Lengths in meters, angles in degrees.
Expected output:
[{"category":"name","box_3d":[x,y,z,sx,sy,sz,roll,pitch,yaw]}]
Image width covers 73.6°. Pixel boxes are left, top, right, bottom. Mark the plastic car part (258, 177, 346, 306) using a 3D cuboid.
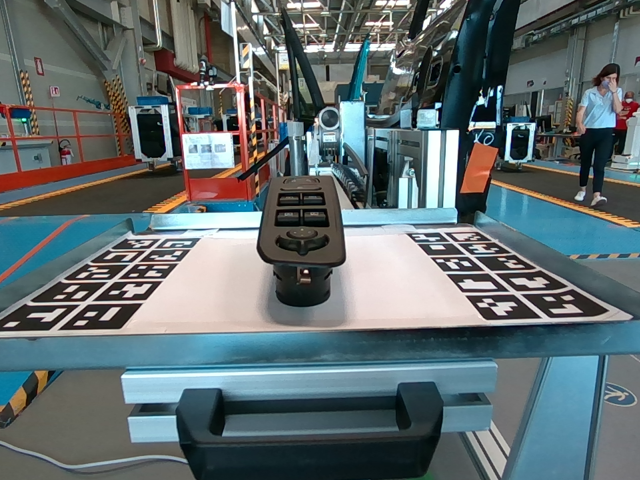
[{"category":"plastic car part","box_3d":[-0.017,-0.006,0.365,0.066,0.067,0.203,5,19,-5]}]
